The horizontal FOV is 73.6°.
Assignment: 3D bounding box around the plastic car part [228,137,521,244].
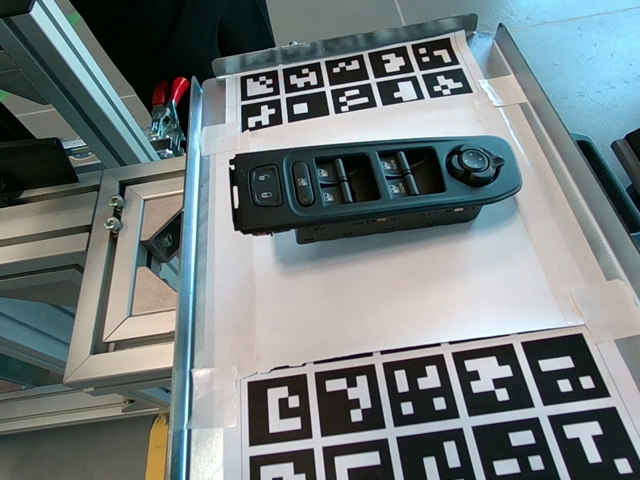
[{"bbox_3d":[0.042,-0.031,0.307,0.203,0.066,0.067,-9,-39,-3],"label":"plastic car part"}]
